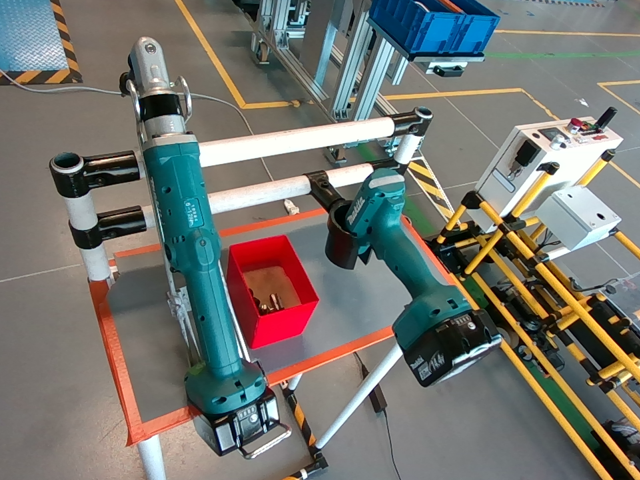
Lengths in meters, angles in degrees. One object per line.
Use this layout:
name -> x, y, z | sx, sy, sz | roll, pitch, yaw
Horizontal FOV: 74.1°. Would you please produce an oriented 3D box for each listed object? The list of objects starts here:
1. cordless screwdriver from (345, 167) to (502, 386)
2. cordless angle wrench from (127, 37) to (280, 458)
cordless screwdriver -> 0.100, 0.050, 0.528 | 0.074, 0.248, 0.159 | -15, -25, -24
cordless angle wrench -> -0.135, 0.007, 0.444 | 0.074, 0.422, 0.098 | -16, 9, -35
